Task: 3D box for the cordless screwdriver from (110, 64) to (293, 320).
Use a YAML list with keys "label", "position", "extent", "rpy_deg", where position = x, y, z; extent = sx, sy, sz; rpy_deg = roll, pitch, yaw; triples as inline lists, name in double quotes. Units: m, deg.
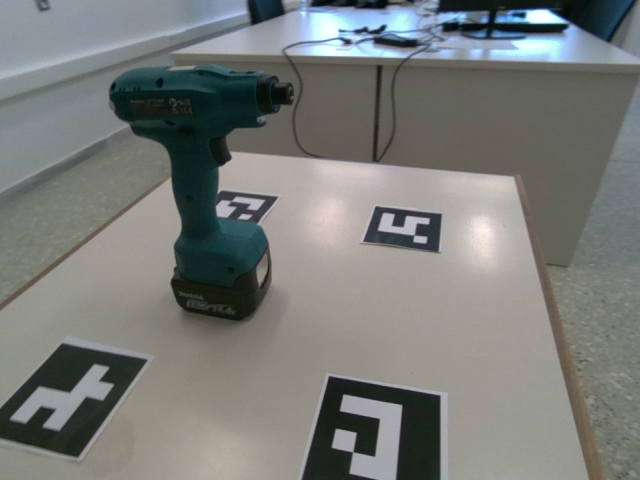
- label: "cordless screwdriver"
  position: [-0.091, -0.038, 0.415]
  extent: [0.160, 0.248, 0.074]
  rpy_deg: [5, 33, 17]
